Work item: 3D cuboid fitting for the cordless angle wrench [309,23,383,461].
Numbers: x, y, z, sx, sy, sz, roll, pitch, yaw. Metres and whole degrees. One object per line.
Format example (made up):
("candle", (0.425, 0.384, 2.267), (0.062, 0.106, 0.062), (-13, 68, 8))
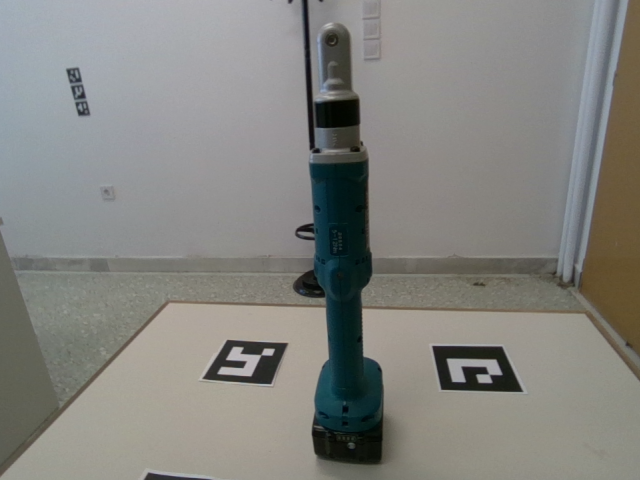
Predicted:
("cordless angle wrench", (0.023, 0.024, 0.416), (0.074, 0.422, 0.097), (0, 20, 10))
